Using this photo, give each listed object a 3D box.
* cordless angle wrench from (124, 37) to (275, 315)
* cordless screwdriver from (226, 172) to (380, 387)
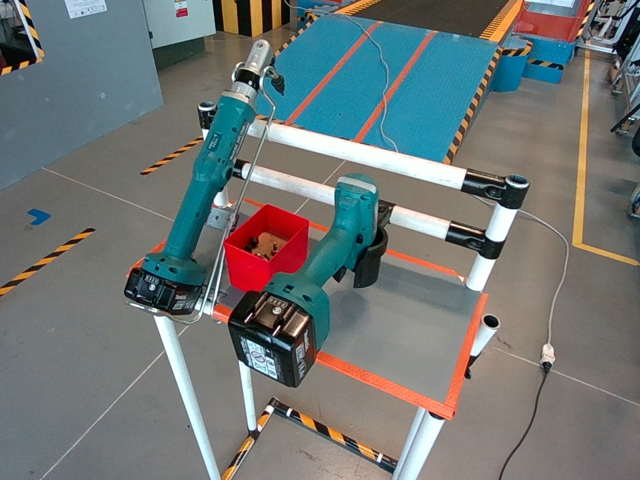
[{"bbox_3d":[-0.154,-0.102,0.619,0.074,0.422,0.098,19,-4,18],"label":"cordless angle wrench"},{"bbox_3d":[0.002,0.051,0.500,0.074,0.159,0.248,20,53,22],"label":"cordless screwdriver"}]
